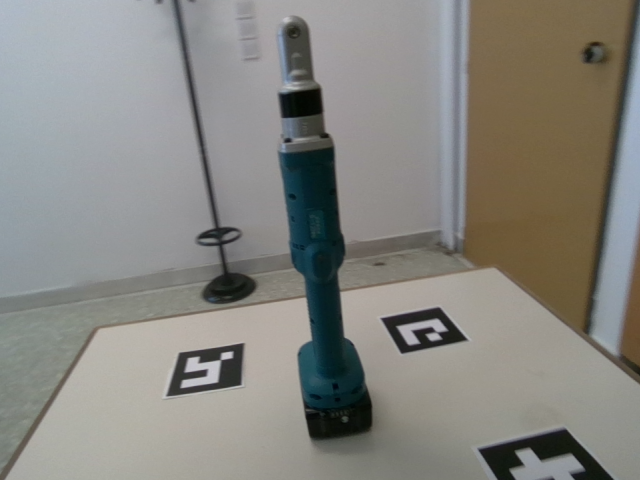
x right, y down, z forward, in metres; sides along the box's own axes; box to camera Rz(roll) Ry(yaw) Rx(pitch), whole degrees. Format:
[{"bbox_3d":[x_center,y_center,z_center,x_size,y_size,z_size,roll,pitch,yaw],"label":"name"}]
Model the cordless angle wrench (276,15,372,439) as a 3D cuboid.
[{"bbox_3d":[-0.003,0.009,0.432,0.074,0.422,0.098,-8,21,-5],"label":"cordless angle wrench"}]
